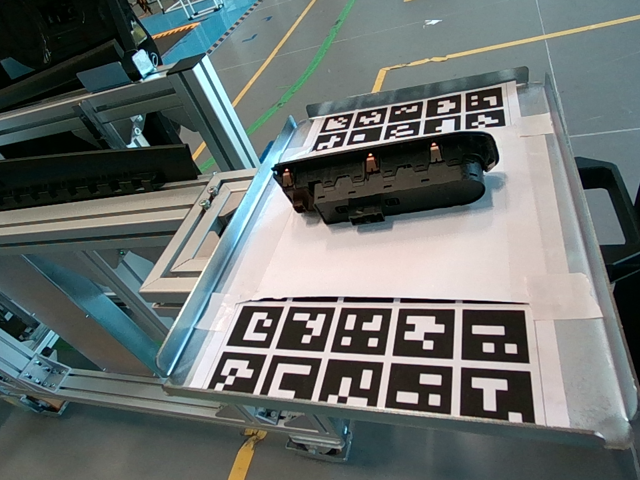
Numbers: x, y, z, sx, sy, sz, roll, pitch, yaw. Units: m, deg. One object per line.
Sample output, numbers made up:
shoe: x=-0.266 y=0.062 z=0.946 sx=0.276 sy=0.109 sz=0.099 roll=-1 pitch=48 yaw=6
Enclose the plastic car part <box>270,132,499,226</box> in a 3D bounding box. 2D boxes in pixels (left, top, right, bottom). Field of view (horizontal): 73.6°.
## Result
plastic car part: x=0.058 y=-0.050 z=0.385 sx=0.204 sy=0.067 sz=0.066 roll=-11 pitch=-37 yaw=12
